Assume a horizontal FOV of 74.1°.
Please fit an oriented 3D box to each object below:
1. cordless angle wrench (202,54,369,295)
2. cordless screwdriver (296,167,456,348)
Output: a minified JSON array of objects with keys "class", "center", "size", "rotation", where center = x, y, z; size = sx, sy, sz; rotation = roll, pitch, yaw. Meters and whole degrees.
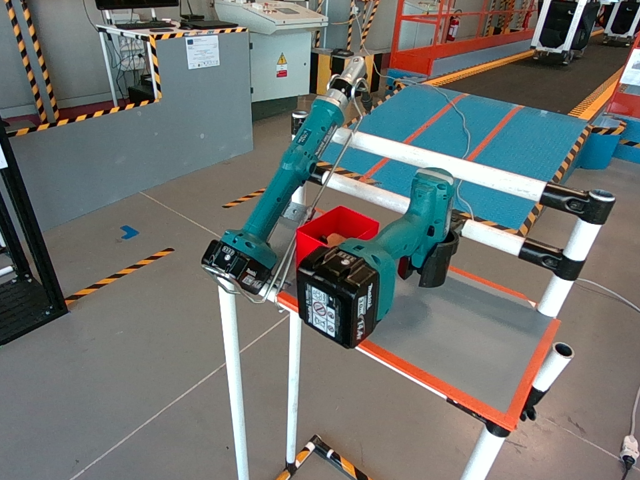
[{"class":"cordless angle wrench","center":[-0.033,-0.120,0.669],"size":[0.074,0.422,0.098],"rotation":[25,-9,28]},{"class":"cordless screwdriver","center":[0.082,0.030,0.512],"size":[0.074,0.159,0.248],"rotation":[25,46,33]}]
